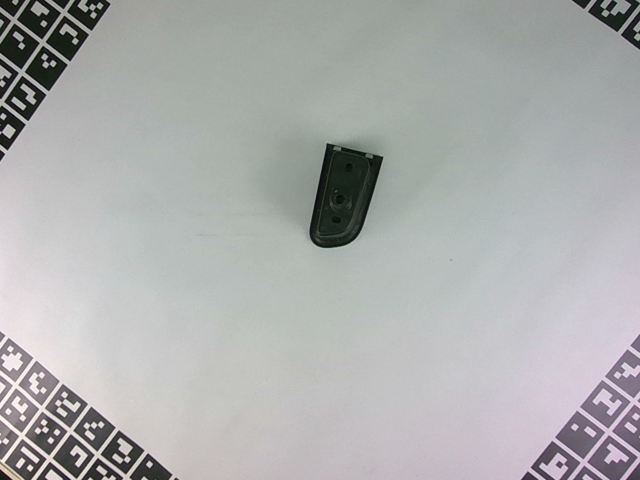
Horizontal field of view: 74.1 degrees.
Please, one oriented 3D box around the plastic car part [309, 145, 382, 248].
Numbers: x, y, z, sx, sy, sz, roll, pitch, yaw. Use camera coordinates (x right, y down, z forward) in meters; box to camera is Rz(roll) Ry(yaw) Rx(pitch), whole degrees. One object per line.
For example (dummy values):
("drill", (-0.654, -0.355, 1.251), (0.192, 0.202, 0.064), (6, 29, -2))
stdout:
("plastic car part", (0.023, -0.047, 0.460), (0.066, 0.116, 0.071), (14, -2, 4))
